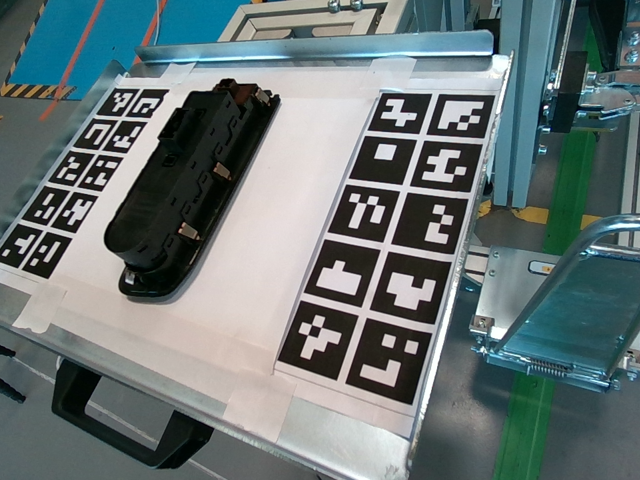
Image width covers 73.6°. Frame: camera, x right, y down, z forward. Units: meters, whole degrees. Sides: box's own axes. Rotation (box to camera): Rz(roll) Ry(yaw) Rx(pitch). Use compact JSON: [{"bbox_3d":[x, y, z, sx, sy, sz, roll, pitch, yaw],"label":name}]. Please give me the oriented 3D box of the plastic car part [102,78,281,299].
[{"bbox_3d":[-0.098,-0.052,0.324,0.066,0.202,0.067,12,-21,20],"label":"plastic car part"}]
